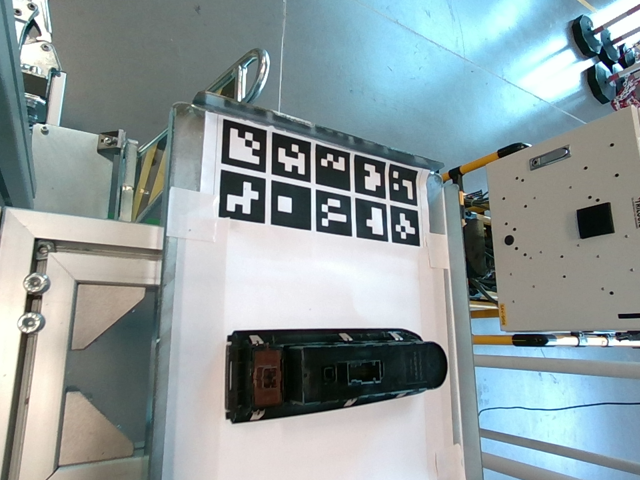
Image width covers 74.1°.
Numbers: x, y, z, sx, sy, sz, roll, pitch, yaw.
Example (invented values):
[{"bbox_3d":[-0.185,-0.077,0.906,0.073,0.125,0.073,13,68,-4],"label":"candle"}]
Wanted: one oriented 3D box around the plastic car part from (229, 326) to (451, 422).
[{"bbox_3d":[0.032,0.101,0.346,0.202,0.066,0.067,7,-22,-34],"label":"plastic car part"}]
